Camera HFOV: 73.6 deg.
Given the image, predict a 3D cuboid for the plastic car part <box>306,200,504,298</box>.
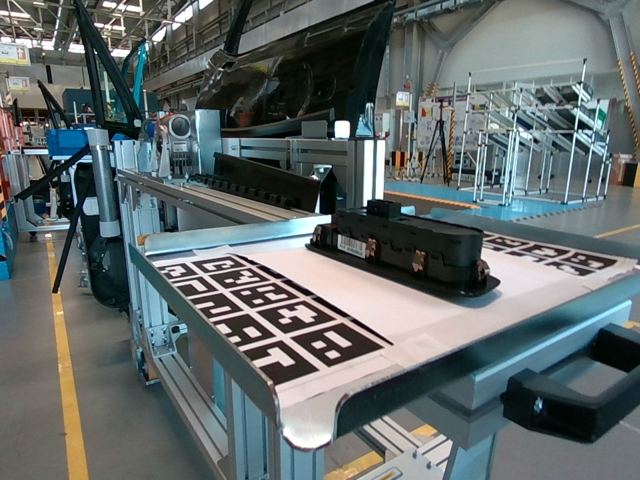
[{"bbox_3d":[0.072,0.001,0.388,0.066,0.067,0.204,-1,15,-37],"label":"plastic car part"}]
